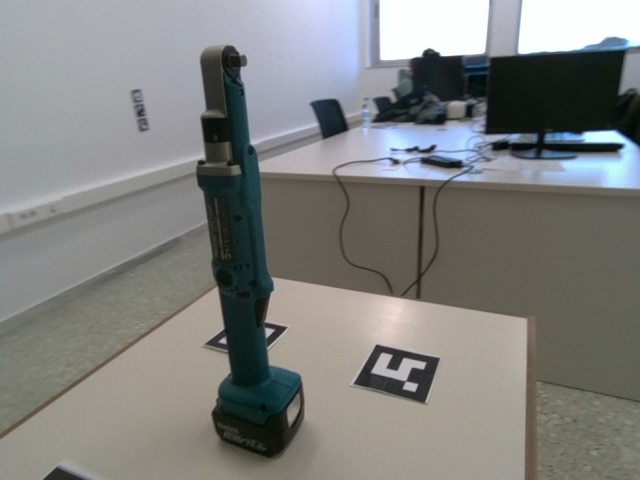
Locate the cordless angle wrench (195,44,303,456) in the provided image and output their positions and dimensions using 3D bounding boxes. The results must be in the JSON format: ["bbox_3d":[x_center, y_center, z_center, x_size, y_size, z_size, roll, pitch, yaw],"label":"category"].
[{"bbox_3d":[-0.082,0.029,0.444,0.099,0.422,0.074,6,22,23],"label":"cordless angle wrench"}]
